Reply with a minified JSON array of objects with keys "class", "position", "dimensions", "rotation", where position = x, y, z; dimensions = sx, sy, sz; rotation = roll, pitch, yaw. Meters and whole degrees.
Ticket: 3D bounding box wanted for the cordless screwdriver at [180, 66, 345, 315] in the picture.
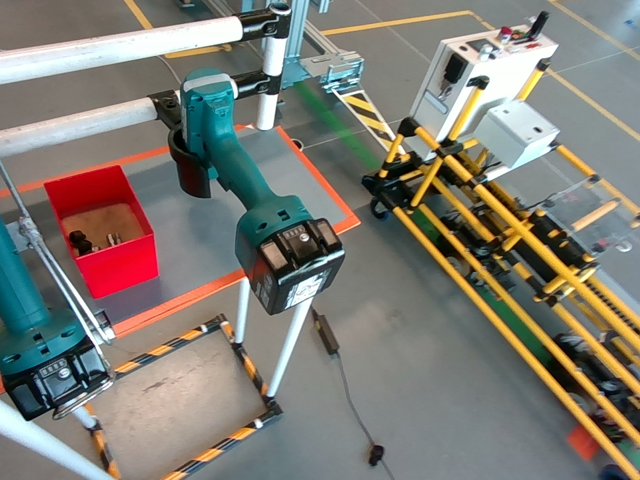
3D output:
[{"class":"cordless screwdriver","position":[-0.081,-0.041,0.456],"dimensions":[0.074,0.248,0.160],"rotation":[-24,-18,-26]}]
